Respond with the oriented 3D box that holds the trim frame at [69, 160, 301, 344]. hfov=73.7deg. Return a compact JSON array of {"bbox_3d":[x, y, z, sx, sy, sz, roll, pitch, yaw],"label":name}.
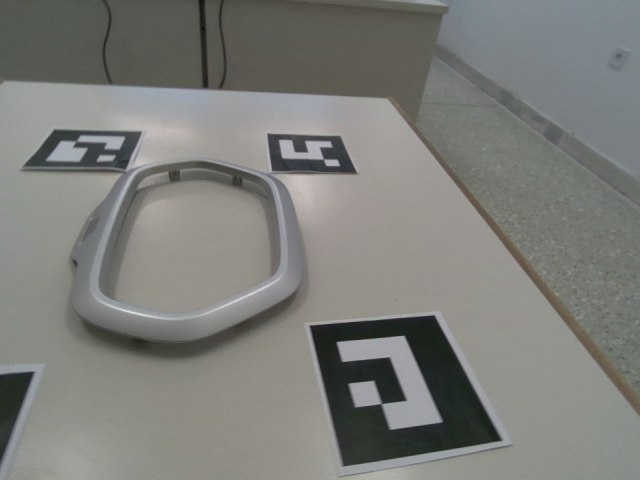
[{"bbox_3d":[-0.112,-0.009,0.367,0.183,0.027,0.249,-1,39,-11],"label":"trim frame"}]
